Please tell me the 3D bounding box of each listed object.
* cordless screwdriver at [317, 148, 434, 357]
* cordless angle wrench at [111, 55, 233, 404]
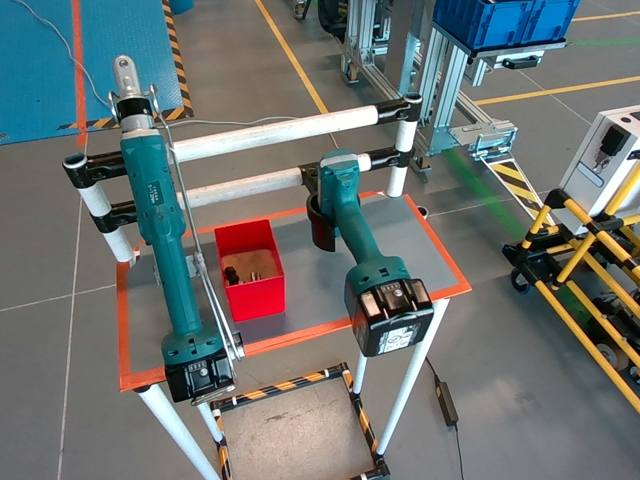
[{"bbox_3d":[0.050,0.022,0.540,0.074,0.248,0.160,-13,-32,-10],"label":"cordless screwdriver"},{"bbox_3d":[-0.196,-0.020,0.525,0.074,0.423,0.098,-14,1,-19],"label":"cordless angle wrench"}]
